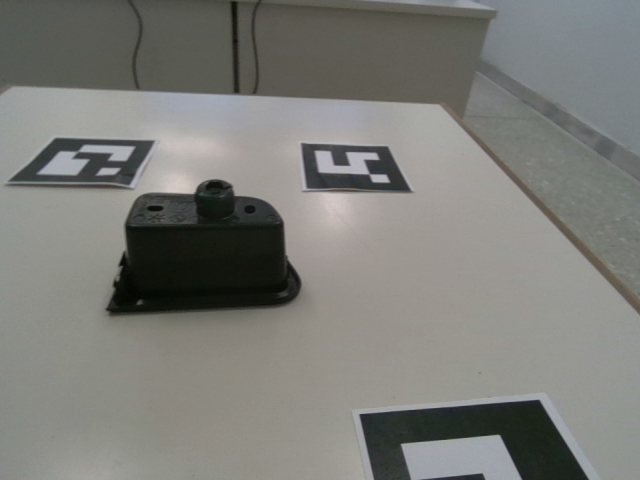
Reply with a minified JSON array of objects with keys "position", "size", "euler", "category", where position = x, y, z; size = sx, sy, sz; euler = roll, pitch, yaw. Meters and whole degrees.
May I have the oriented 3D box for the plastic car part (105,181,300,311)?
[{"position":[-0.071,-0.002,0.266],"size":[0.116,0.071,0.066],"euler":[-3,37,-5],"category":"plastic car part"}]
